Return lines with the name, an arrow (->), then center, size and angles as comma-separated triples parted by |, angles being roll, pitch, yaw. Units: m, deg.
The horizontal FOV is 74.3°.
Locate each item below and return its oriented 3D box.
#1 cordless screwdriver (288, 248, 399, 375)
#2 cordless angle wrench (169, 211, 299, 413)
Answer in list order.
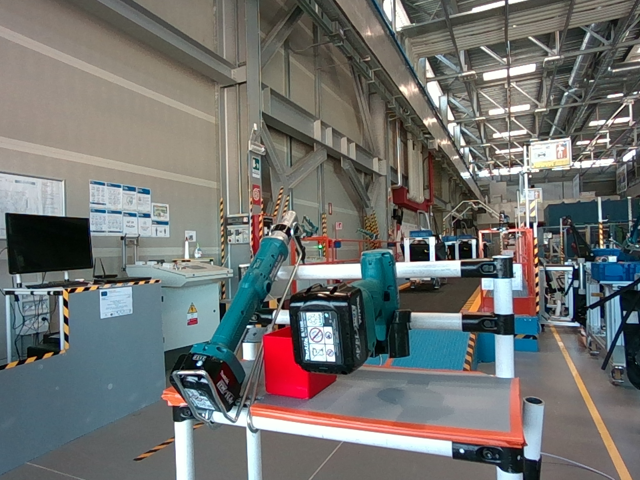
cordless screwdriver -> 0.053, 0.108, 0.556 | 0.074, 0.159, 0.248 | -4, 7, 26
cordless angle wrench -> -0.115, 0.085, 0.746 | 0.074, 0.098, 0.421 | 2, 43, 20
